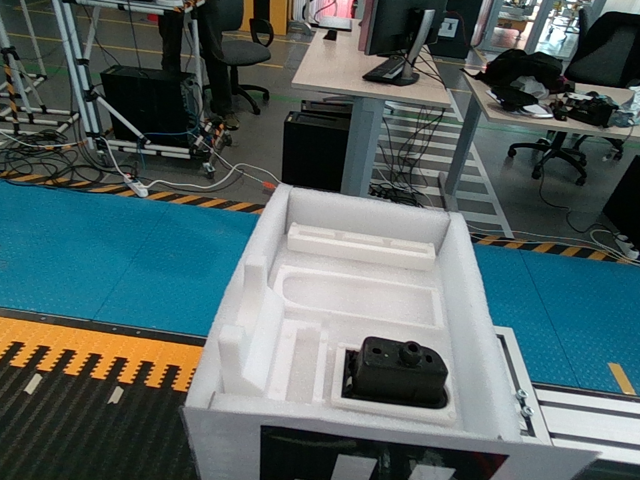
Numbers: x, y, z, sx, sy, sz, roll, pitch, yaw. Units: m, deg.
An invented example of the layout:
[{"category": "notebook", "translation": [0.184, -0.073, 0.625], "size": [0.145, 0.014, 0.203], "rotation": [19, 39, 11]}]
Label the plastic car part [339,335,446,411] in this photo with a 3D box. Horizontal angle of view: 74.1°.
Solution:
[{"category": "plastic car part", "translation": [0.084, 0.137, 0.461], "size": [0.117, 0.071, 0.066], "rotation": [7, 38, 4]}]
